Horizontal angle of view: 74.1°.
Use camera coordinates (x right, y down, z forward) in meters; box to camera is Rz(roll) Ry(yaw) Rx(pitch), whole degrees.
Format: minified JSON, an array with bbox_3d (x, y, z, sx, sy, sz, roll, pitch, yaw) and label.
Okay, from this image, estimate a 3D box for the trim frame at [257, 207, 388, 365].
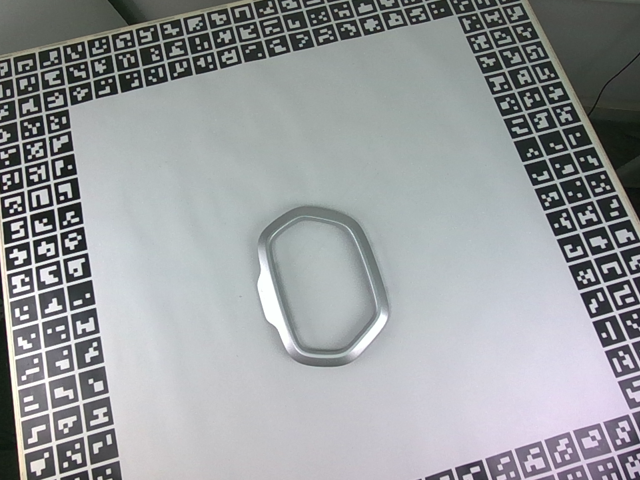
[{"bbox_3d":[-0.004,0.063,0.641,0.184,0.248,0.027,-20,-16,1],"label":"trim frame"}]
